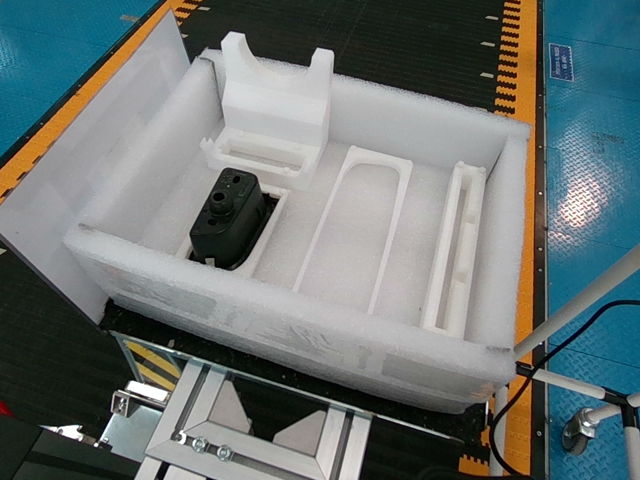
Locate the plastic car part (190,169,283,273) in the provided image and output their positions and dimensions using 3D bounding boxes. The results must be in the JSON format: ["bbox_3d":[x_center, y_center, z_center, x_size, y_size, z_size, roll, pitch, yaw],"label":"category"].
[{"bbox_3d":[-0.095,-0.028,0.444,0.066,0.116,0.071,17,-32,13],"label":"plastic car part"}]
